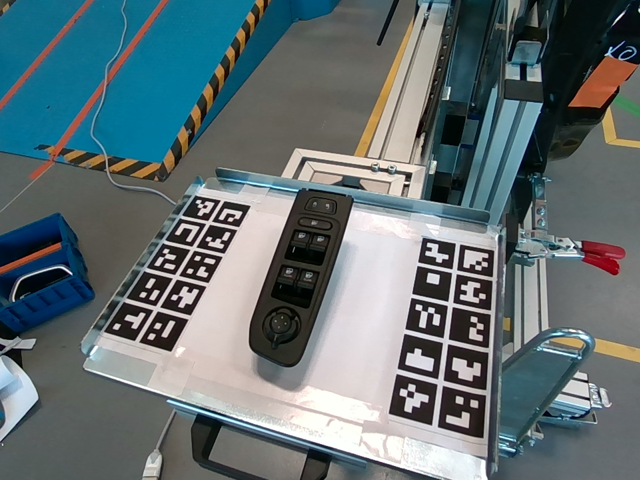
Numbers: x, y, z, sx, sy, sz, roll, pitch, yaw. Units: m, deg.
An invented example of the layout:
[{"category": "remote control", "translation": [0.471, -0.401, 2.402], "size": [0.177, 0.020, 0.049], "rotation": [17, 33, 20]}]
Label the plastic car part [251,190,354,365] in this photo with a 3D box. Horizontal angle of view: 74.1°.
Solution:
[{"category": "plastic car part", "translation": [-0.019, 0.039, 0.460], "size": [0.066, 0.202, 0.067], "rotation": [15, -34, 6]}]
